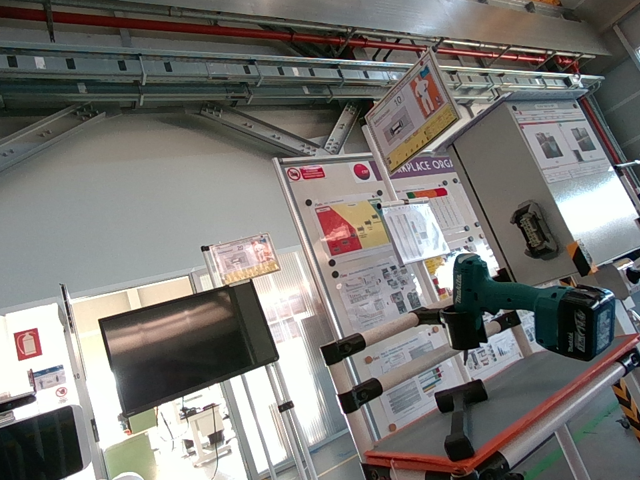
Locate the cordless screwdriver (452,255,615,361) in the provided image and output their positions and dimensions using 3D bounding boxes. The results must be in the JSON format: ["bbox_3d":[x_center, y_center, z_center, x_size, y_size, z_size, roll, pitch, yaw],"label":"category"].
[{"bbox_3d":[0.323,0.123,0.686,0.074,0.159,0.249,-14,19,-34],"label":"cordless screwdriver"}]
